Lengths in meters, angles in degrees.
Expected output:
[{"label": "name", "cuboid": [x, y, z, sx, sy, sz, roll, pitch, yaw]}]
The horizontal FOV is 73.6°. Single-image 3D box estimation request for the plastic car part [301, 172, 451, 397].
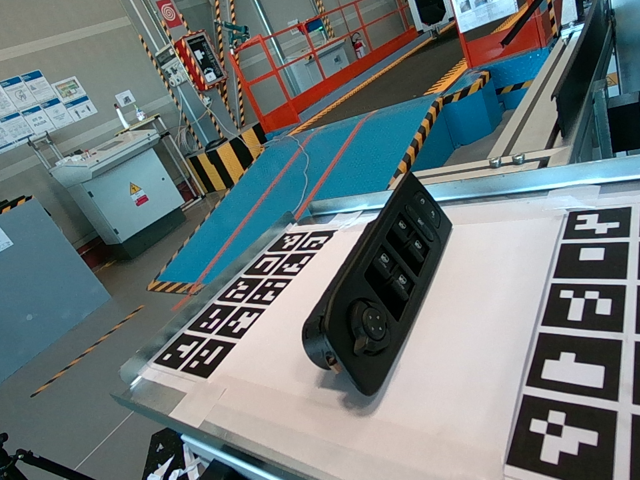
[{"label": "plastic car part", "cuboid": [0.041, 0.024, 0.320, 0.067, 0.066, 0.202, -23, 20, 36]}]
